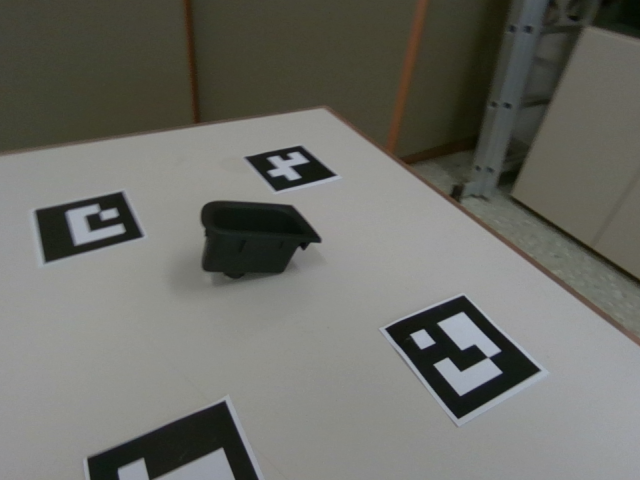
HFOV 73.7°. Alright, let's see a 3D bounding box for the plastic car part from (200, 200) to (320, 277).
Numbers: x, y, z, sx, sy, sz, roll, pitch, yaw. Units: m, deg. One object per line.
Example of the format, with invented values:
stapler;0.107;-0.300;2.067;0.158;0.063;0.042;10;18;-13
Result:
plastic car part;-0.071;0.005;0.421;0.115;0.071;0.066;-1;40;-39
